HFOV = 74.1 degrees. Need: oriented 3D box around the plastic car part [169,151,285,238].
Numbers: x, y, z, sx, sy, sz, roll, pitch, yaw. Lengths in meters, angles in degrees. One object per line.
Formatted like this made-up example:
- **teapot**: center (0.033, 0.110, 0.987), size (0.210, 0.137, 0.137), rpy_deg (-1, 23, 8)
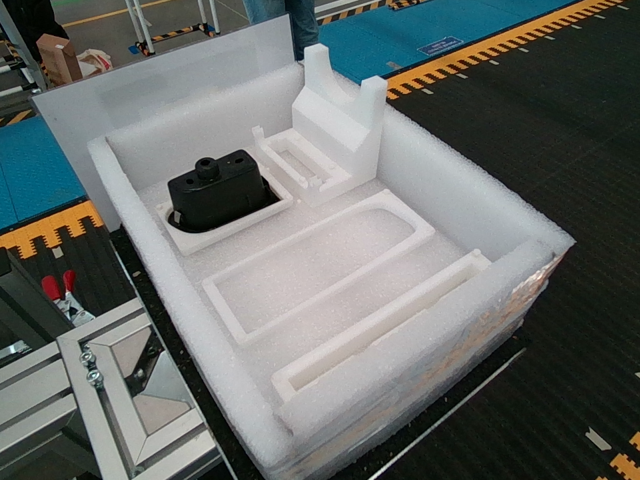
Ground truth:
- **plastic car part**: center (-0.106, -0.055, 0.451), size (0.116, 0.071, 0.066), rpy_deg (-25, 50, -22)
